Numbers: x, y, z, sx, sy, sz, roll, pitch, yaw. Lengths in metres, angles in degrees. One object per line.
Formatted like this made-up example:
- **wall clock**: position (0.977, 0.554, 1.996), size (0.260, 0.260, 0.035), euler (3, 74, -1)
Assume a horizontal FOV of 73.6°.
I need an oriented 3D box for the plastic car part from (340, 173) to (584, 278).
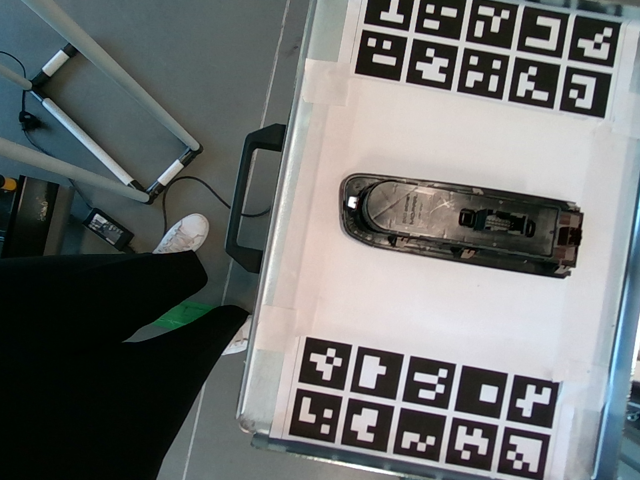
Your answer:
- **plastic car part**: position (0.115, -0.013, 0.338), size (0.203, 0.066, 0.067), euler (9, 5, 2)
